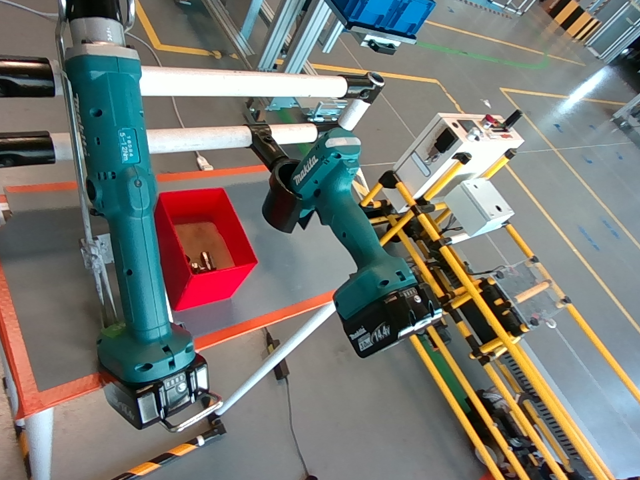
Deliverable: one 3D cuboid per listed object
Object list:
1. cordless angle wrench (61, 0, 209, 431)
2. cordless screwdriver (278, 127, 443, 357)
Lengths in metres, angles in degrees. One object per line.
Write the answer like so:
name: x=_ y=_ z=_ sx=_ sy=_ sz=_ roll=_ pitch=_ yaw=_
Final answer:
cordless angle wrench: x=-0.176 y=-0.046 z=0.372 sx=0.098 sy=0.423 sz=0.074 roll=7 pitch=16 yaw=40
cordless screwdriver: x=0.028 y=0.011 z=0.506 sx=0.074 sy=0.248 sz=0.160 roll=-13 pitch=-17 yaw=-38
